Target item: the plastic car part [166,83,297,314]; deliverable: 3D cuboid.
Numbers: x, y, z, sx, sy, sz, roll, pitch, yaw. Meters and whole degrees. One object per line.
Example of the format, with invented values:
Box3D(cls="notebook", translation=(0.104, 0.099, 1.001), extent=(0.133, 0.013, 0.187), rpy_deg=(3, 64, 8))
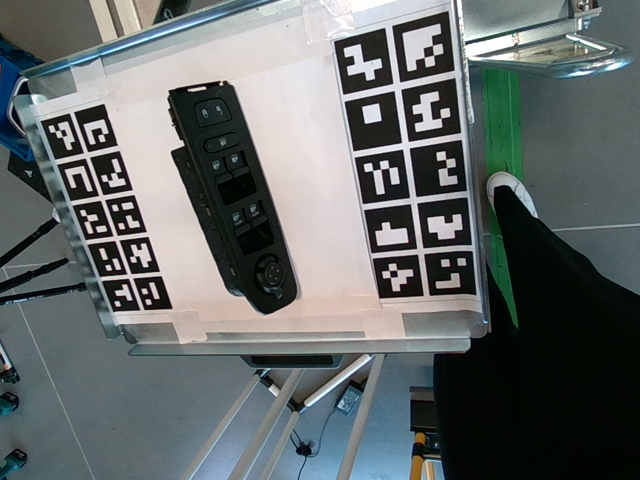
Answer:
Box3D(cls="plastic car part", translation=(-0.081, -0.026, 0.373), extent=(0.067, 0.203, 0.066), rpy_deg=(-14, 15, 33))
